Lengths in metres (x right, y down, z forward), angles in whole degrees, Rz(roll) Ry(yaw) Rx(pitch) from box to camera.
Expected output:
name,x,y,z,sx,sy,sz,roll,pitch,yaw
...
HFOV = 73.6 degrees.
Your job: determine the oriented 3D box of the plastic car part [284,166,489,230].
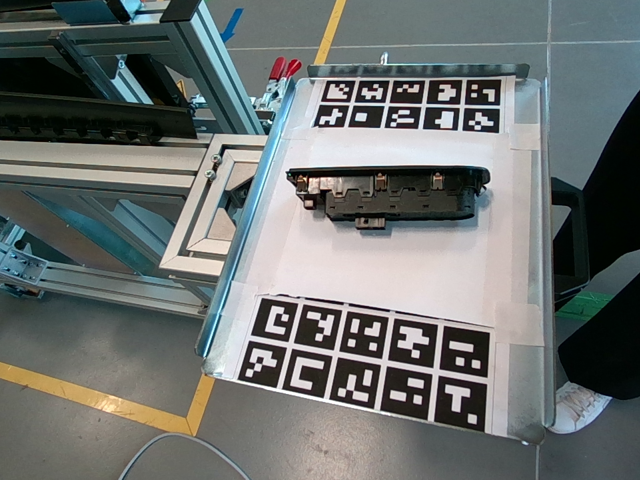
name,x,y,z,sx,sy,sz,roll,pitch,yaw
plastic car part,0.068,-0.045,0.432,0.203,0.067,0.066,-4,-16,9
